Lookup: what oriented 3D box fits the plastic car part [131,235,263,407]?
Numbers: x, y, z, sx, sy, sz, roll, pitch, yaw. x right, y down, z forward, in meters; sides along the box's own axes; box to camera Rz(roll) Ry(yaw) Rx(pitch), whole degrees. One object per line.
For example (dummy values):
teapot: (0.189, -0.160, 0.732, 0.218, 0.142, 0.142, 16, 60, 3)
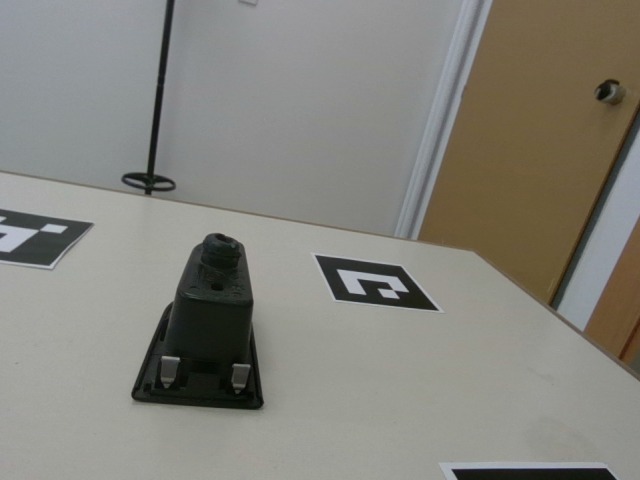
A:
plastic car part: (-0.065, 0.035, 0.261, 0.066, 0.071, 0.117, 9, 22, -13)
